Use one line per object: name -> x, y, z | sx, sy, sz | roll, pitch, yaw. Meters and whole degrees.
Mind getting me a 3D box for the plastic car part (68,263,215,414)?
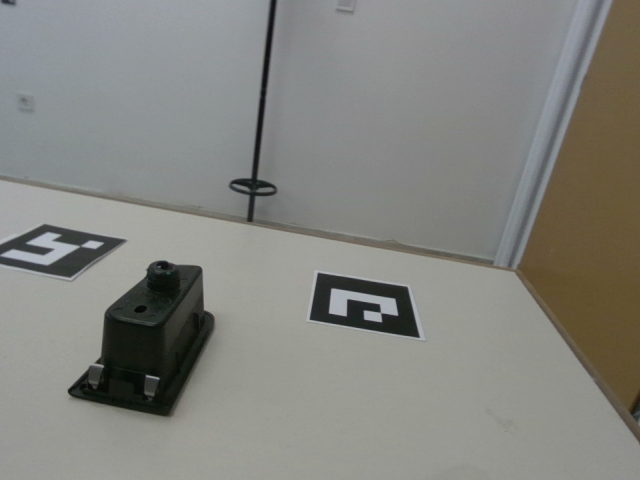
plastic car part -> -0.117, 0.055, 0.310 | 0.066, 0.071, 0.116 | 10, 25, 3
